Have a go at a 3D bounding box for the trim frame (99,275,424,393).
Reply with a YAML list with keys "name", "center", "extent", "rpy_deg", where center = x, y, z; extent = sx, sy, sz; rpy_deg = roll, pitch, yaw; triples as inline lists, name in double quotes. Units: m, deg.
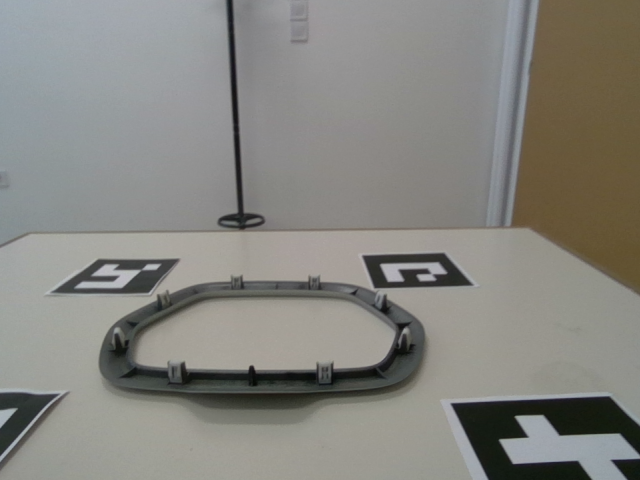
- name: "trim frame"
  center: [-0.044, 0.067, 0.340]
  extent: [0.248, 0.027, 0.184]
  rpy_deg: [2, 19, 2]
